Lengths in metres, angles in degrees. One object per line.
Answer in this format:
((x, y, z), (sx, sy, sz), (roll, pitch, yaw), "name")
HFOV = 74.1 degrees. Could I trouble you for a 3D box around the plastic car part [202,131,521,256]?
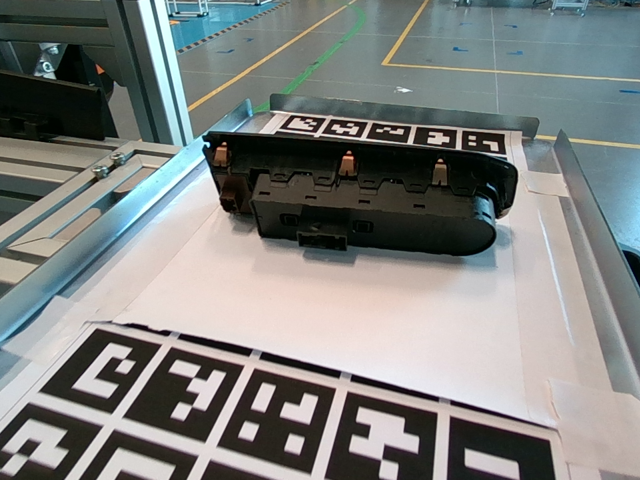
((0.025, -0.026, 0.267), (0.203, 0.067, 0.066), (2, -41, 4), "plastic car part")
